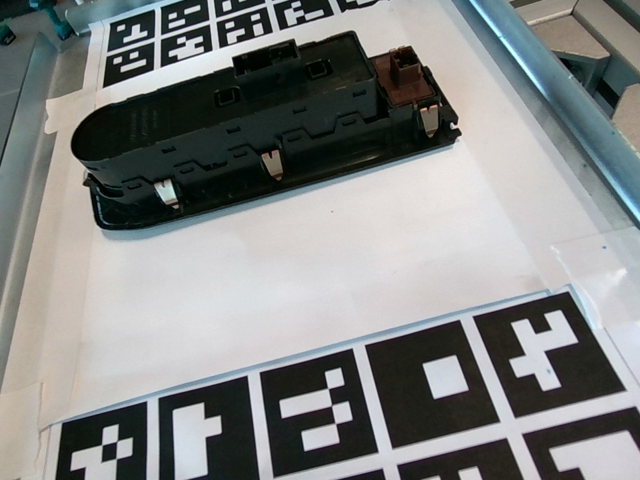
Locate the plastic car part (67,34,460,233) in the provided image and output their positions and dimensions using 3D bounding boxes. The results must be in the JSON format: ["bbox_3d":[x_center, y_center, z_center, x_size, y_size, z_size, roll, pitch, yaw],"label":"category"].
[{"bbox_3d":[-0.036,-0.056,0.216,0.203,0.066,0.067,-18,-27,4],"label":"plastic car part"}]
